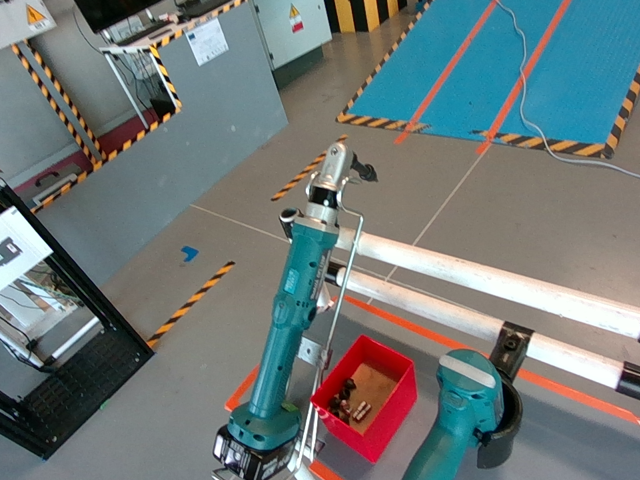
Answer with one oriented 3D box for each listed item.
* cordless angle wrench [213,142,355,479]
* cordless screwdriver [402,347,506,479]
[{"bbox_3d":[-0.030,0.085,0.530,0.074,0.422,0.098,18,4,32],"label":"cordless angle wrench"},{"bbox_3d":[0.095,0.230,0.375,0.074,0.248,0.159,20,-27,39],"label":"cordless screwdriver"}]
